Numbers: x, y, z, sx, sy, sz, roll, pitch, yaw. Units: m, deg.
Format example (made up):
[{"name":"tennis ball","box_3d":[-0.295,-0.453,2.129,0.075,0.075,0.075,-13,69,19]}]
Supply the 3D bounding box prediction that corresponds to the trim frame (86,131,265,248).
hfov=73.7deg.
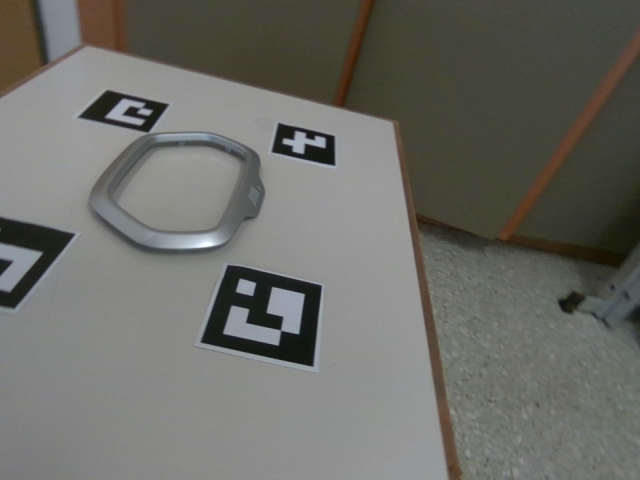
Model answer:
[{"name":"trim frame","box_3d":[-0.160,-0.072,0.513,0.184,0.027,0.248,10,38,-2]}]
